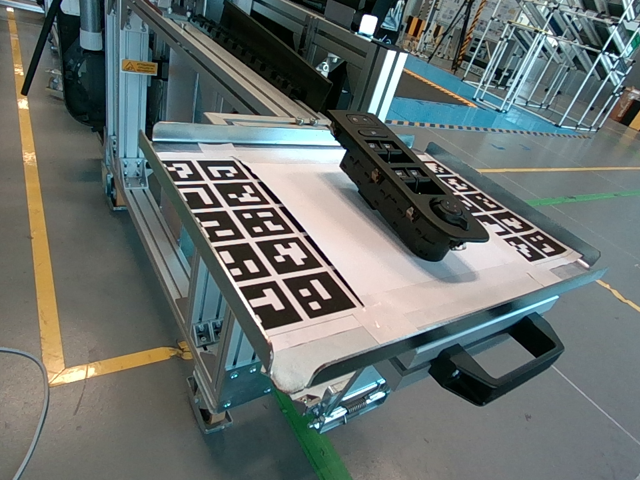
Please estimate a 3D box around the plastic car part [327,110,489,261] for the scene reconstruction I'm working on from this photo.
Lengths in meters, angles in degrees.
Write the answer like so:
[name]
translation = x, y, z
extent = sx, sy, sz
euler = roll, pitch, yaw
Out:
[plastic car part]
translation = 0.072, -0.053, 0.418
extent = 0.066, 0.067, 0.203
euler = -1, 40, -41
